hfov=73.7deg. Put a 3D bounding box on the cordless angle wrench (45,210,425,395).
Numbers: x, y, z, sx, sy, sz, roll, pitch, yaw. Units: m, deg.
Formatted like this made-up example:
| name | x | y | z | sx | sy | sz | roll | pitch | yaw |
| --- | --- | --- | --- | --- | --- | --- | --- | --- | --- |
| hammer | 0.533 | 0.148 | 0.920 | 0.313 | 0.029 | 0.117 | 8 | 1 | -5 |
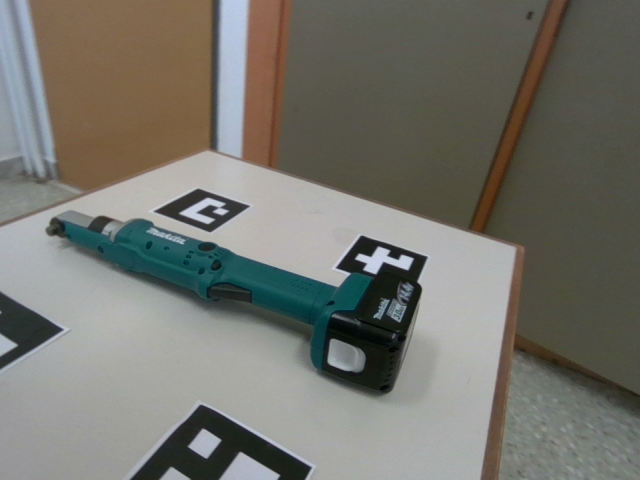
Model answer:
| name | x | y | z | sx | sy | sz | roll | pitch | yaw |
| --- | --- | --- | --- | --- | --- | --- | --- | --- | --- |
| cordless angle wrench | -0.115 | 0.031 | 0.439 | 0.426 | 0.074 | 0.097 | 16 | 30 | 19 |
